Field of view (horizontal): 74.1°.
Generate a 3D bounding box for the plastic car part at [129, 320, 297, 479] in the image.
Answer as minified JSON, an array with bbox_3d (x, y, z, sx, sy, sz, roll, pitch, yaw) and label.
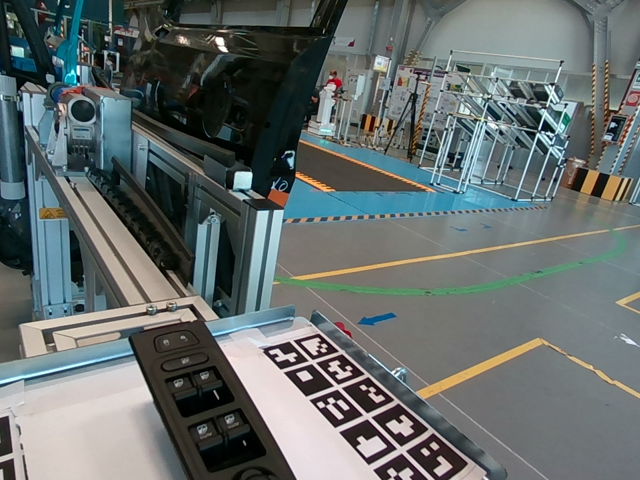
[{"bbox_3d":[-0.083,0.145,0.313,0.066,0.067,0.204,4,24,-43],"label":"plastic car part"}]
